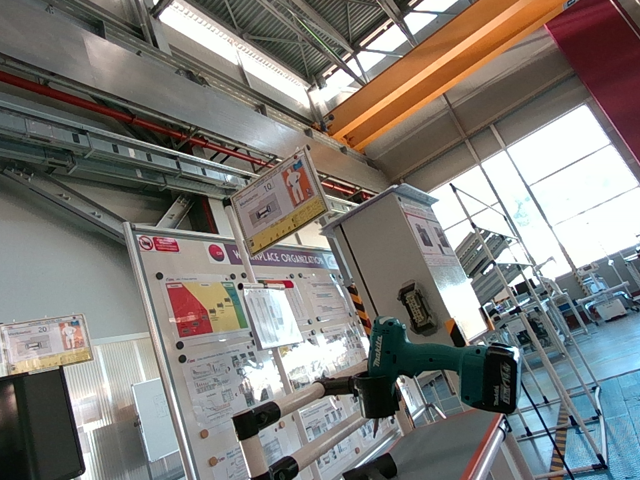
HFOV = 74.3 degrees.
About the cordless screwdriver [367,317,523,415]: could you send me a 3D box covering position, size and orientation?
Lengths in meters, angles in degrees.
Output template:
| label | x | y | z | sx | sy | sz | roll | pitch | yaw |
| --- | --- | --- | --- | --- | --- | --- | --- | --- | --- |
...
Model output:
| label | x | y | z | sx | sy | sz | roll | pitch | yaw |
| --- | --- | --- | --- | --- | --- | --- | --- | --- | --- |
| cordless screwdriver | 0.194 | 0.226 | 0.695 | 0.249 | 0.159 | 0.074 | 6 | 0 | 31 |
